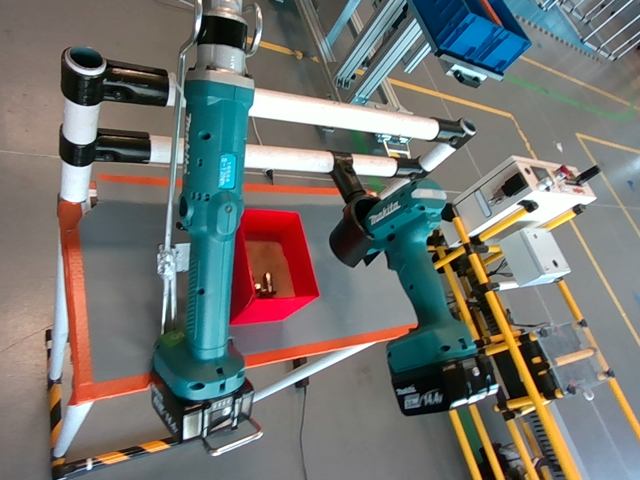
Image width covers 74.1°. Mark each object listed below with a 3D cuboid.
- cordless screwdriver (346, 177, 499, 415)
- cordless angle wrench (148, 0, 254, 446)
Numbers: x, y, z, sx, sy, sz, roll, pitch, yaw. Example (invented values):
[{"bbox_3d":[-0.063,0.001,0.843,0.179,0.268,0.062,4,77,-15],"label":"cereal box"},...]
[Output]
[{"bbox_3d":[0.100,0.068,0.497,0.074,0.248,0.159,-1,-19,-32],"label":"cordless screwdriver"},{"bbox_3d":[-0.099,-0.030,0.379,0.074,0.423,0.098,-4,16,-41],"label":"cordless angle wrench"}]
